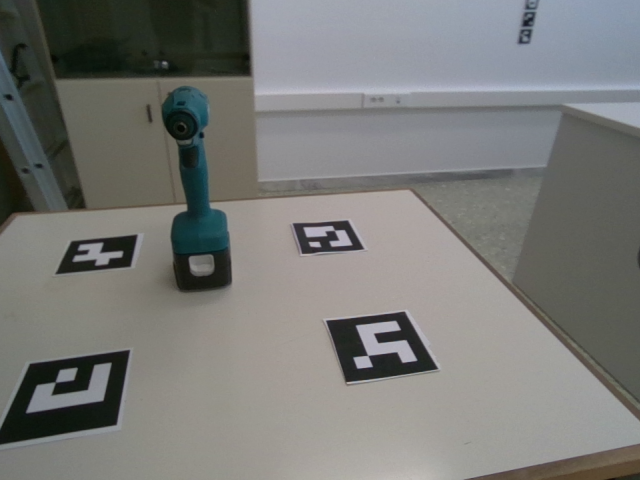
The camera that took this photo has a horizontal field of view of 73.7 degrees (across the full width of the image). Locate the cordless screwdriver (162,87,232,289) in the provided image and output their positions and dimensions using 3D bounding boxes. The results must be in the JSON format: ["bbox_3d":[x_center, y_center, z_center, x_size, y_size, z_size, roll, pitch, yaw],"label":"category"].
[{"bbox_3d":[-0.154,-0.053,0.528,0.074,0.249,0.160,-5,26,-11],"label":"cordless screwdriver"}]
